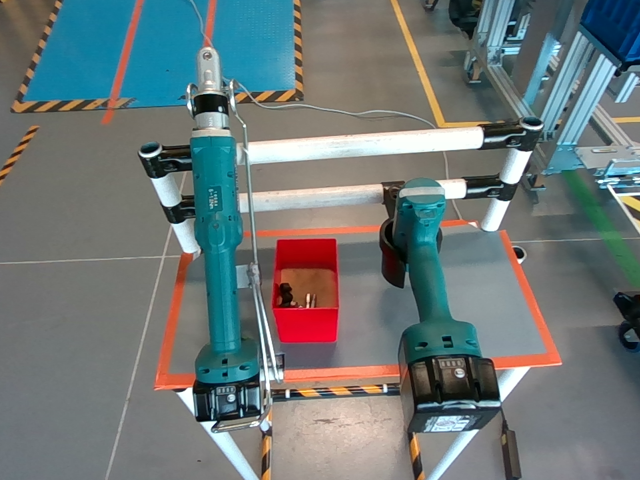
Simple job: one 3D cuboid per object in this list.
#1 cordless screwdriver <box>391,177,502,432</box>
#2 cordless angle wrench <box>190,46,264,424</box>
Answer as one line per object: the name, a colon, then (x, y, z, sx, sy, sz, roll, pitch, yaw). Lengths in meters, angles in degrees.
cordless screwdriver: (0.114, 0.074, 0.461, 0.074, 0.248, 0.159, -2, -32, 1)
cordless angle wrench: (-0.116, -0.011, 0.492, 0.074, 0.423, 0.098, -4, 1, -5)
